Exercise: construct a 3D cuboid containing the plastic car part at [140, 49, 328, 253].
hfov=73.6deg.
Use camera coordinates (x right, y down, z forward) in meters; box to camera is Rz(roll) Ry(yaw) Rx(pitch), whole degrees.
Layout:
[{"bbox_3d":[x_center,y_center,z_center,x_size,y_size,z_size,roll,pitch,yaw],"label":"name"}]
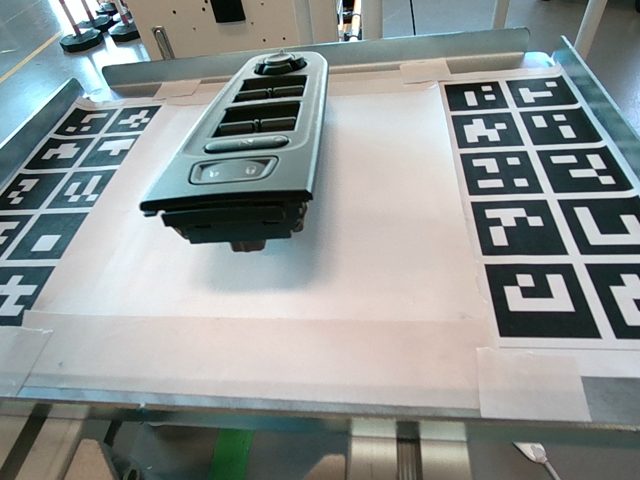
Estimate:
[{"bbox_3d":[-0.026,-0.059,0.246,0.066,0.067,0.202,-9,42,11],"label":"plastic car part"}]
